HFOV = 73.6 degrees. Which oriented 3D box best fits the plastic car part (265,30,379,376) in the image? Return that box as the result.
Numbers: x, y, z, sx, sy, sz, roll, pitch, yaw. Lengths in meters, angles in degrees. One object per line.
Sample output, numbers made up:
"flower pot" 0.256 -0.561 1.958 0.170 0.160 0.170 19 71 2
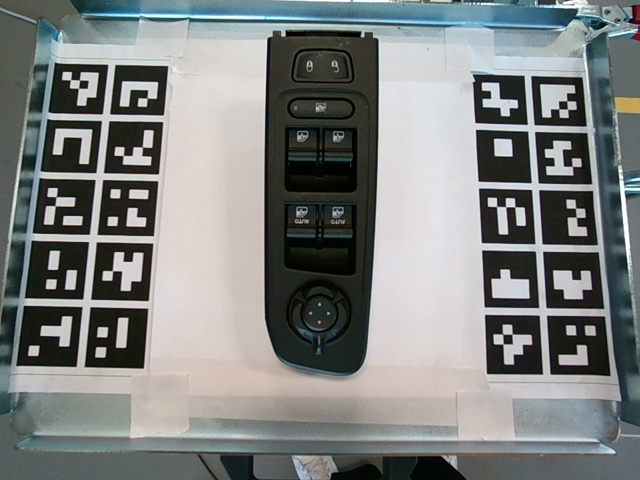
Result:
"plastic car part" -0.002 -0.021 0.269 0.066 0.202 0.067 1 -6 -9
